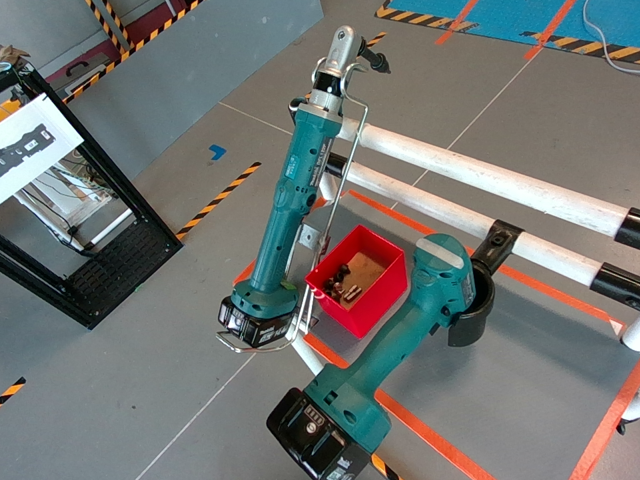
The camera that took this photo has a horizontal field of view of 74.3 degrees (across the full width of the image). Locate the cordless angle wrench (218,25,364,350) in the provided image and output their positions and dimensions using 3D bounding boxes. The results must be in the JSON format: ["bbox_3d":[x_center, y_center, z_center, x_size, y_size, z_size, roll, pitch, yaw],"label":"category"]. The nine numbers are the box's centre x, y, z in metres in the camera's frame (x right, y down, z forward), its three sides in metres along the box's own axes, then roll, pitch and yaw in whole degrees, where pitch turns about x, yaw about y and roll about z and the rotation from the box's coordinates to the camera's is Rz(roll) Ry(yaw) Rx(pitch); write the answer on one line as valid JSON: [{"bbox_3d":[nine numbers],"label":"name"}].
[{"bbox_3d":[-0.030,-0.060,0.555,0.074,0.423,0.098,28,17,30],"label":"cordless angle wrench"}]

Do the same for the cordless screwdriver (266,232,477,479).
[{"bbox_3d":[0.072,0.123,0.425,0.074,0.248,0.159,33,-12,37],"label":"cordless screwdriver"}]
